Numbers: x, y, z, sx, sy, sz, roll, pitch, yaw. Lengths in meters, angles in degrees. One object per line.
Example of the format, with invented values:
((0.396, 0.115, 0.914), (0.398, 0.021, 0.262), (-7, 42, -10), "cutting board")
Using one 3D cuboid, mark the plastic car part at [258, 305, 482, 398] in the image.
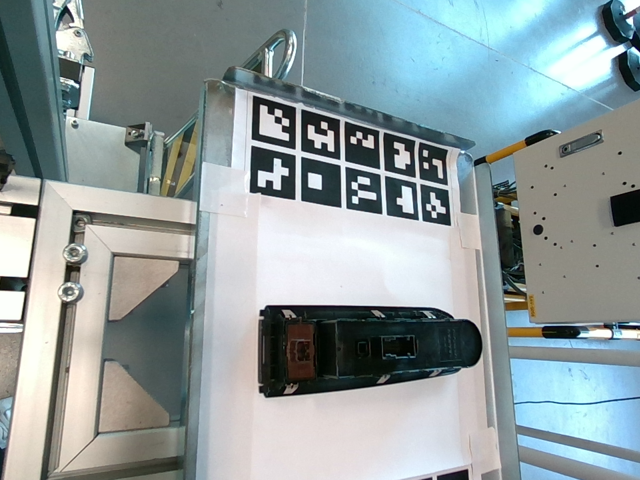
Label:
((0.054, 0.082, 0.340), (0.202, 0.066, 0.067), (7, -22, -32), "plastic car part")
